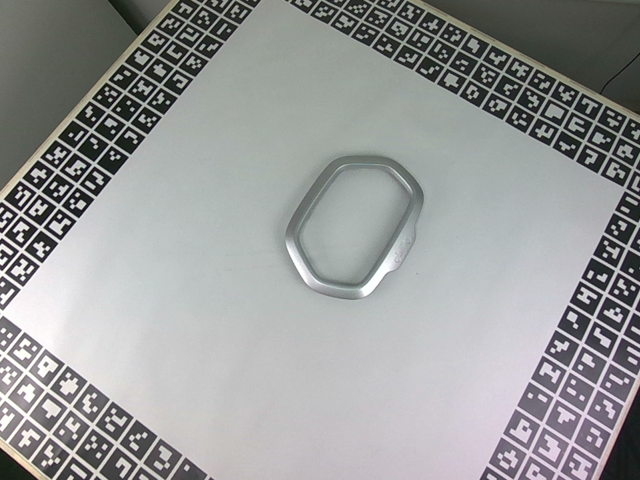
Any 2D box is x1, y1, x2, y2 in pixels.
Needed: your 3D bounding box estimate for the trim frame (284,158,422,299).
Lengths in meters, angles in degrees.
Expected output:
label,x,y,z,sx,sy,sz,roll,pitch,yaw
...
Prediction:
label,x,y,z,sx,sy,sz,roll,pitch,yaw
trim frame,0.055,-0.025,0.662,0.184,0.247,0.027,29,-17,11
